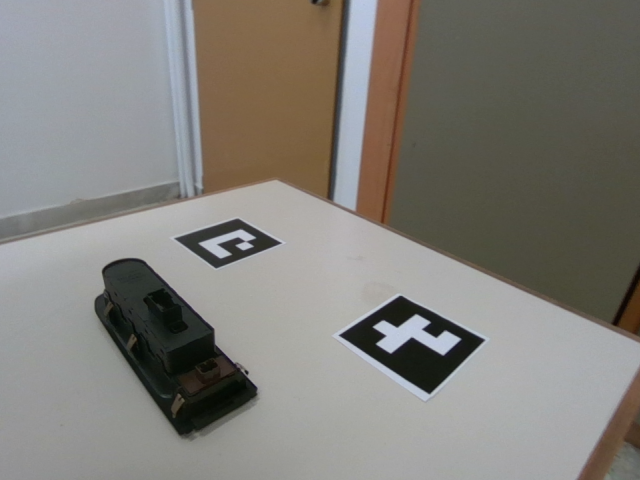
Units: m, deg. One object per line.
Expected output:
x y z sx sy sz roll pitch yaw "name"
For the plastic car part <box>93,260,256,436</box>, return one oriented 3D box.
-0.141 0.071 0.365 0.066 0.067 0.205 -27 36 -36 "plastic car part"
